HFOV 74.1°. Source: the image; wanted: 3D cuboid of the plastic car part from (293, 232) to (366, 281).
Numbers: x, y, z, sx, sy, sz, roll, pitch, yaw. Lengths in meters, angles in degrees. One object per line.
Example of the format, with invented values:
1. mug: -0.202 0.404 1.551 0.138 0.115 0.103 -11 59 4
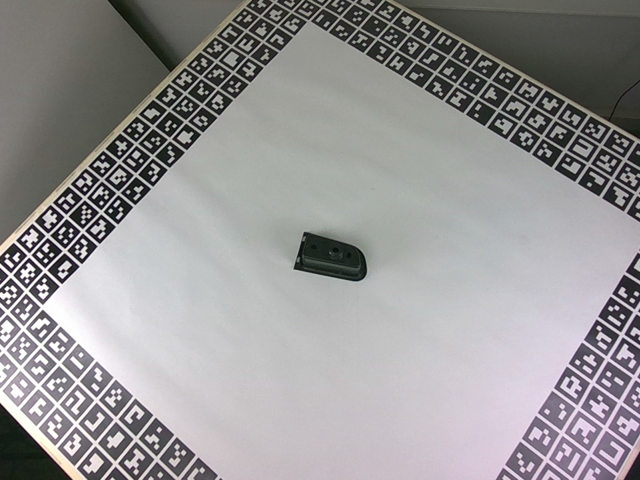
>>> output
1. plastic car part: 0.018 0.023 0.673 0.117 0.066 0.071 13 -13 10
